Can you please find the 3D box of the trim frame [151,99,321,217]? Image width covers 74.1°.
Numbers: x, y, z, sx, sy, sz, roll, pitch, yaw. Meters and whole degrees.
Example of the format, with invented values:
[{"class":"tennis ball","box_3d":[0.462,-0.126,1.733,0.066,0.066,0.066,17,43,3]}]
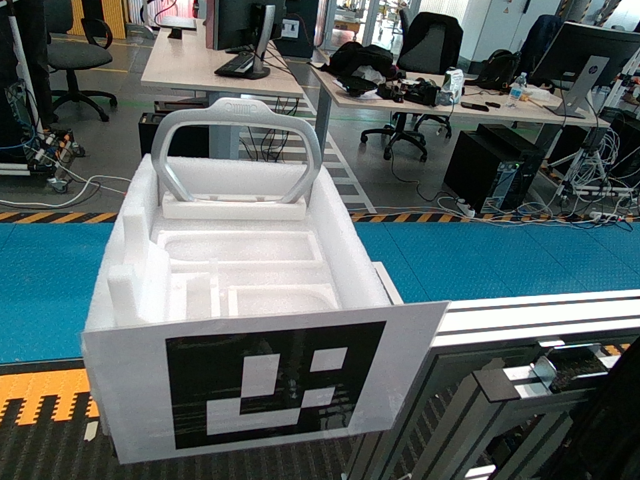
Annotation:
[{"class":"trim frame","box_3d":[-0.119,-0.114,0.633,0.248,0.184,0.027,0,36,-13]}]
